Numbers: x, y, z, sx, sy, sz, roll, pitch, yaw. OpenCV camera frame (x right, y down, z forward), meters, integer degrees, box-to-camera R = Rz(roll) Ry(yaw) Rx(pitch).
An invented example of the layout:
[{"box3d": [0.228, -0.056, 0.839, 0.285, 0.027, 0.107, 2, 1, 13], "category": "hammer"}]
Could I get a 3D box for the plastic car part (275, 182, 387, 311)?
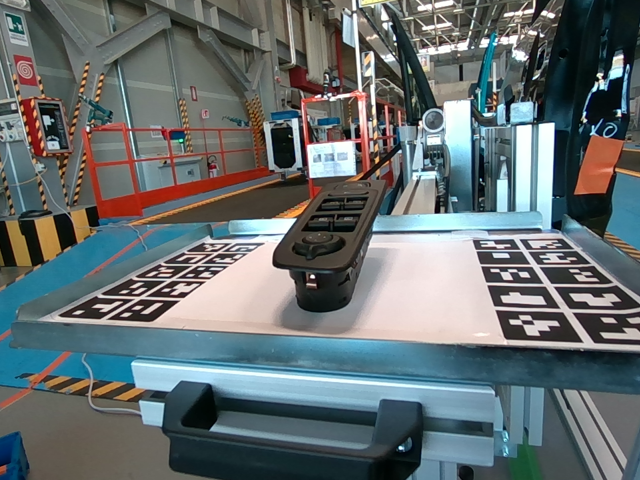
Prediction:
[{"box3d": [0.014, -0.001, 0.362, 0.066, 0.067, 0.202, 6, 20, 12], "category": "plastic car part"}]
